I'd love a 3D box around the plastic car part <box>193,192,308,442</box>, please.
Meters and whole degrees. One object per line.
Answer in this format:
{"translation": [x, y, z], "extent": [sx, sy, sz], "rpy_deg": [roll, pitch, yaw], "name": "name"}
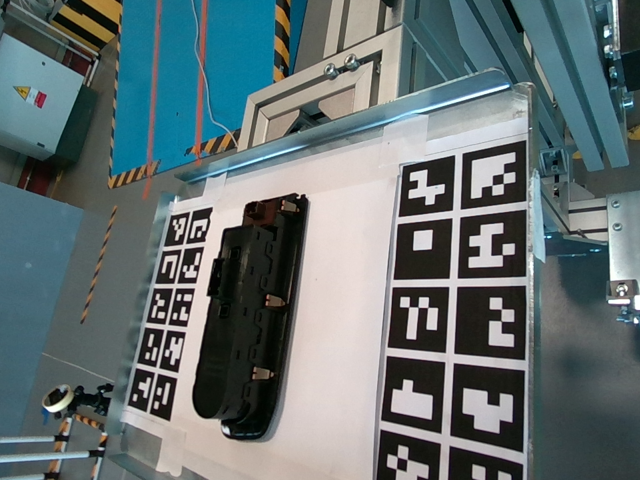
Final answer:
{"translation": [-0.057, 0.054, 0.339], "extent": [0.067, 0.202, 0.067], "rpy_deg": [-5, -17, 34], "name": "plastic car part"}
